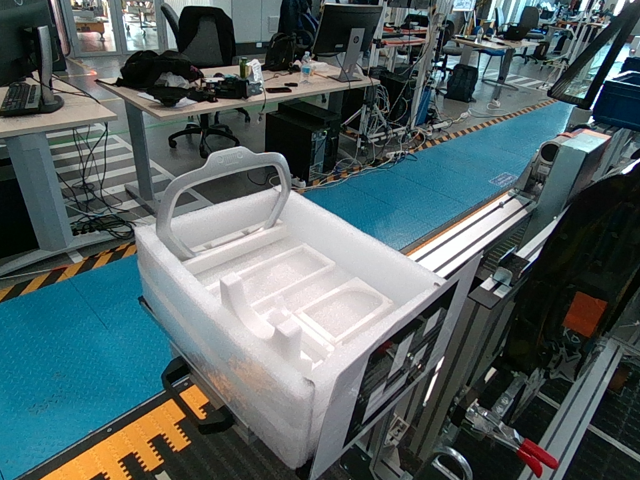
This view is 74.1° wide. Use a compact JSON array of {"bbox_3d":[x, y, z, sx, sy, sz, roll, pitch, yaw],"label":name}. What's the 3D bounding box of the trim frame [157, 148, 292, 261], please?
[{"bbox_3d":[-0.145,-0.057,0.686,0.247,0.184,0.027,-22,48,-34],"label":"trim frame"}]
